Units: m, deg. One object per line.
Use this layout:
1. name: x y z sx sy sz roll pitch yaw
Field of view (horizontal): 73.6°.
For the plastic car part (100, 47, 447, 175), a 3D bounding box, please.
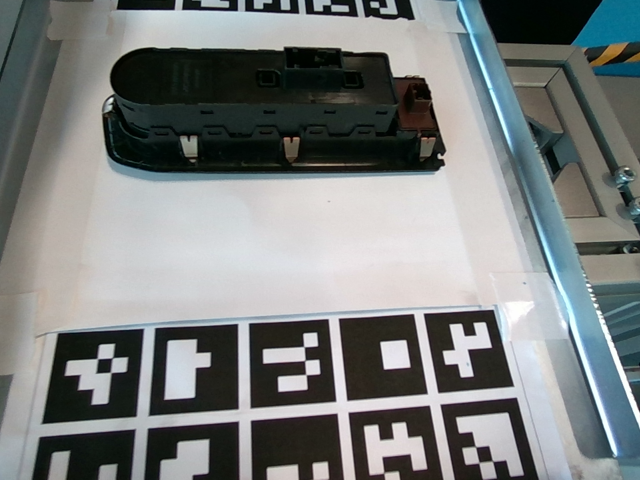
1. plastic car part: -0.024 -0.074 0.240 0.203 0.066 0.067 -4 -19 -5
